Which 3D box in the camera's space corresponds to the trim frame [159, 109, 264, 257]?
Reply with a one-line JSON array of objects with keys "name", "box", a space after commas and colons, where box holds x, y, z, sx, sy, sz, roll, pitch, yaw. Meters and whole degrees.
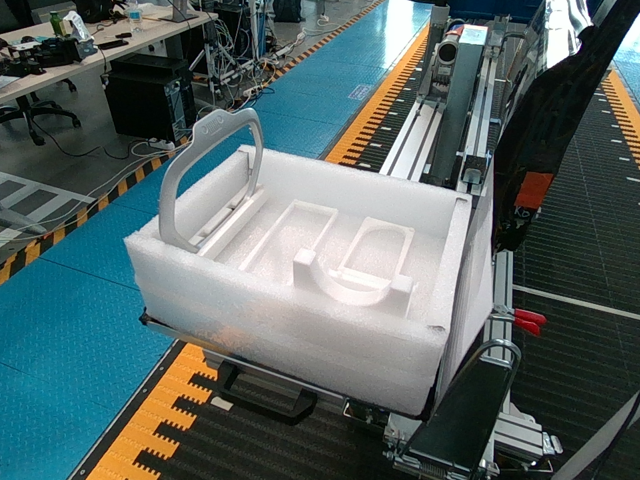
[{"name": "trim frame", "box": [-0.142, -0.085, 0.594, 0.027, 0.184, 0.247, 22, 45, 15]}]
